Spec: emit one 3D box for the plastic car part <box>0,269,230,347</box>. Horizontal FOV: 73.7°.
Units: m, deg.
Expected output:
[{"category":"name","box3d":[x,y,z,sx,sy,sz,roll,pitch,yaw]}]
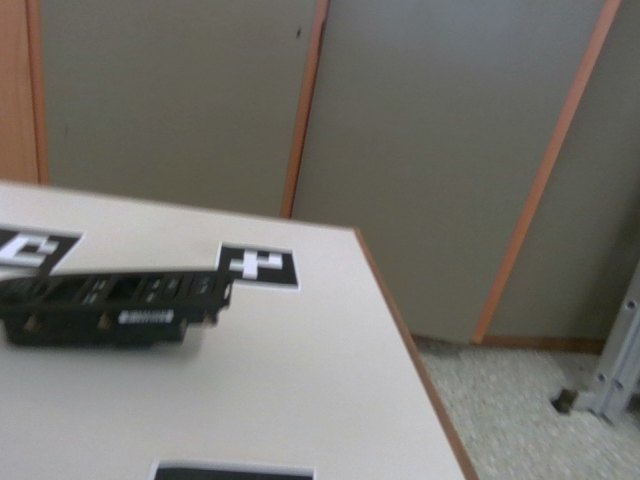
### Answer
[{"category":"plastic car part","box3d":[-0.182,0.059,0.365,0.202,0.067,0.066,4,34,-9]}]
